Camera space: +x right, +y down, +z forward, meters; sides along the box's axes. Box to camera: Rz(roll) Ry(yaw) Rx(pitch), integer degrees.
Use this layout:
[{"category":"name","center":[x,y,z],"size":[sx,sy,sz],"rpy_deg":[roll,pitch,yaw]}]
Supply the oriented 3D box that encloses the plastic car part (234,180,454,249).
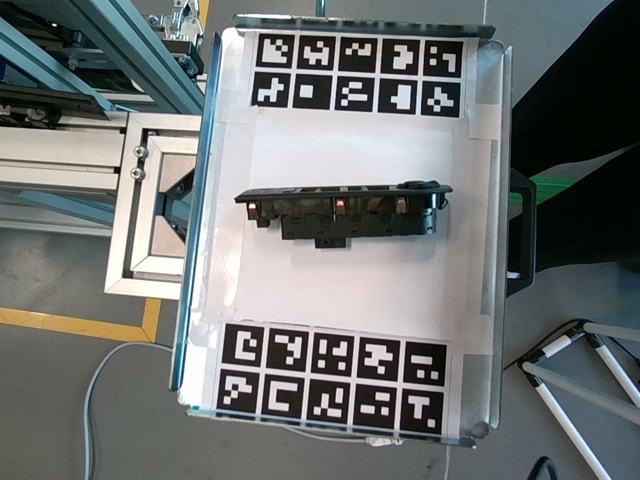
[{"category":"plastic car part","center":[0.026,-0.026,0.406],"size":[0.203,0.067,0.066],"rpy_deg":[-6,5,3]}]
